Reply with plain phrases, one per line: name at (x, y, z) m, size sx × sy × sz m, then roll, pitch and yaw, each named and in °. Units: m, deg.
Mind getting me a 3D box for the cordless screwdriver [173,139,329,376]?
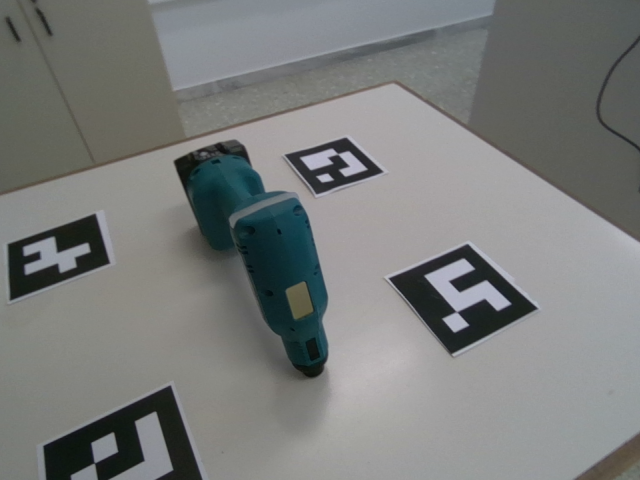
cordless screwdriver at (-0.063, 0.003, 0.399) m, size 0.074 × 0.159 × 0.250 m, roll -23°, pitch 32°, yaw -16°
